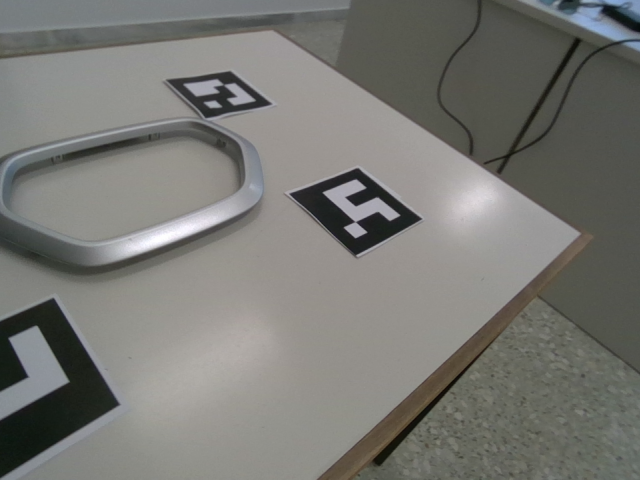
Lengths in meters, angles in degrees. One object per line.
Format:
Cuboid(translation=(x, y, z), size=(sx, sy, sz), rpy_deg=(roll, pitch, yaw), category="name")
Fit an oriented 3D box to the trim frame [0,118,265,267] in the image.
Cuboid(translation=(-0.164, -0.057, 0.385), size=(0.246, 0.027, 0.185), rpy_deg=(-28, 59, -36), category="trim frame")
